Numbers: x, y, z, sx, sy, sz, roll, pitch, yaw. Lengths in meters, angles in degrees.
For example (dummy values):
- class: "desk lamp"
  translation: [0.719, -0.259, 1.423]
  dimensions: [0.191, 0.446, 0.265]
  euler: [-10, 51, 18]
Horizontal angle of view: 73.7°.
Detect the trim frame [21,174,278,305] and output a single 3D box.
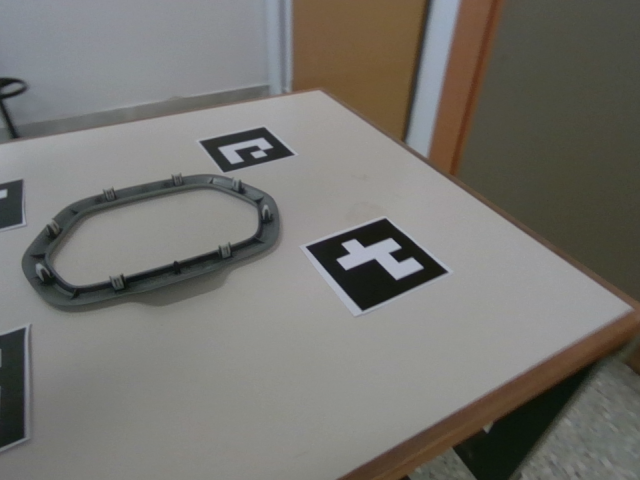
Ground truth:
- class: "trim frame"
  translation: [-0.164, -0.013, 0.434]
  dimensions: [0.246, 0.027, 0.185]
  euler: [-16, 43, -22]
